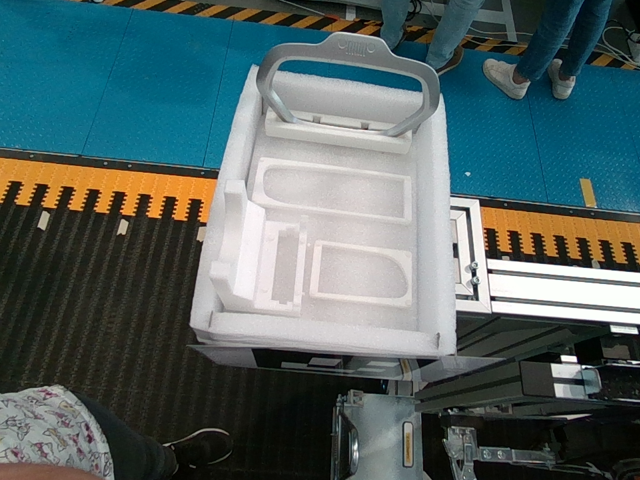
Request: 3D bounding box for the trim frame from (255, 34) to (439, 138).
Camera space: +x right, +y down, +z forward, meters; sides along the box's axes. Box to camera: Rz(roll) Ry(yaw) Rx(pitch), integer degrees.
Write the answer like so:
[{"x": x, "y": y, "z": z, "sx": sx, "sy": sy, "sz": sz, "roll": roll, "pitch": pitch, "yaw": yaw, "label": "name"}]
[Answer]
[{"x": 0.037, "y": -0.198, "z": 0.576, "sx": 0.249, "sy": 0.027, "sz": 0.184, "roll": 8, "pitch": -19, "yaw": -1, "label": "trim frame"}]
